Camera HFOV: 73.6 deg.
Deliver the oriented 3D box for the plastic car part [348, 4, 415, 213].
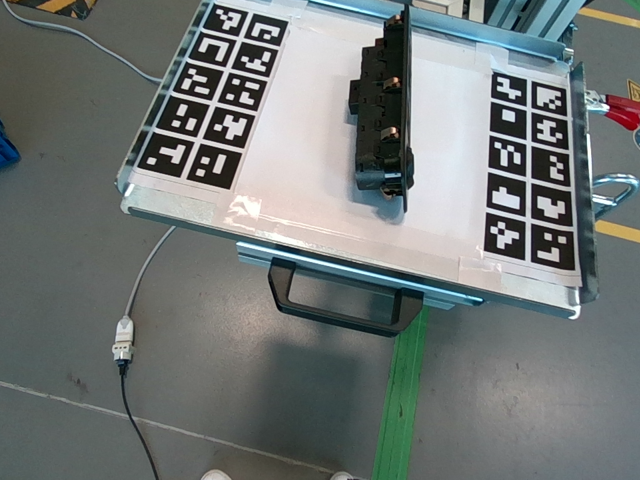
[{"bbox_3d":[0.059,-0.122,0.394,0.067,0.202,0.066,-1,-25,4],"label":"plastic car part"}]
